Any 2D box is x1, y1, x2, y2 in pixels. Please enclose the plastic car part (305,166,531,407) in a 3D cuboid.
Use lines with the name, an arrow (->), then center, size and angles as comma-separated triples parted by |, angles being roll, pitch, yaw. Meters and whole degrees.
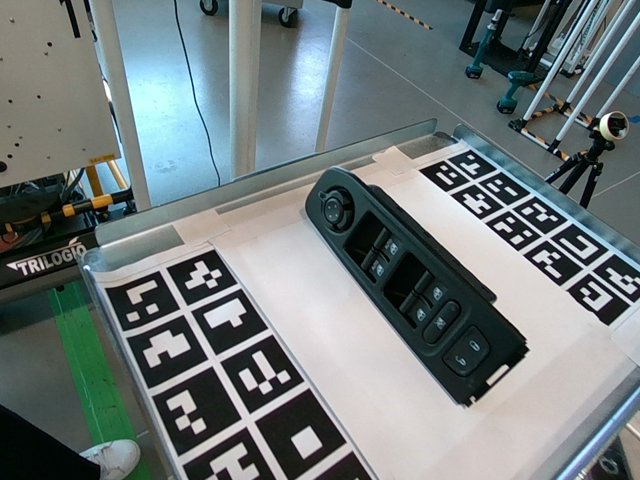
plastic car part -> 0.065, 0.014, 0.321 | 0.066, 0.066, 0.203 | -17, 53, -40
